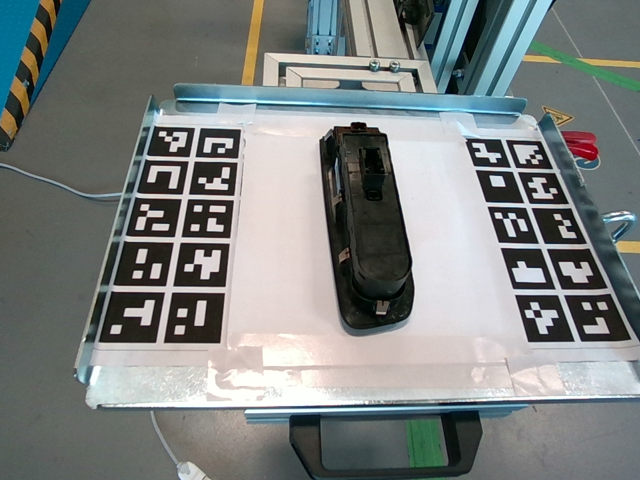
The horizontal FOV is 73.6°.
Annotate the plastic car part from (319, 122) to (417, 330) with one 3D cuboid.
[{"bbox_3d":[0.042,-0.028,0.350,0.066,0.202,0.067,3,-31,-11],"label":"plastic car part"}]
